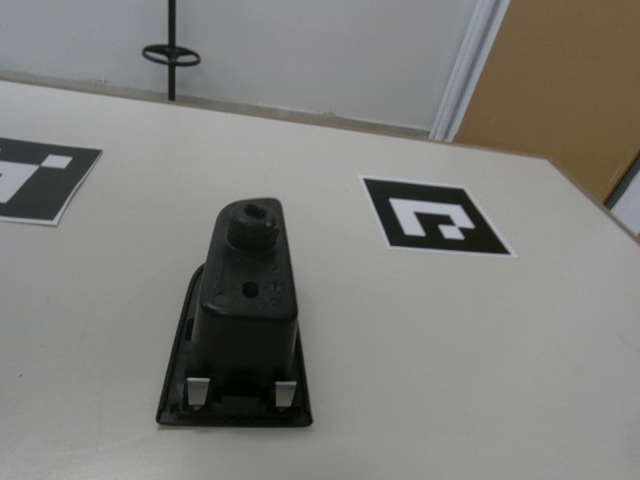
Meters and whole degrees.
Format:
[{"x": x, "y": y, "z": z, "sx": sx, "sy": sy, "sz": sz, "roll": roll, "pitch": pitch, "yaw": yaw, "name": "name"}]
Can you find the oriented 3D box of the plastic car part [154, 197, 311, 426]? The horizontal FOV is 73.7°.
[{"x": -0.036, "y": 0.020, "z": 0.209, "sx": 0.066, "sy": 0.071, "sz": 0.117, "roll": 6, "pitch": 40, "yaw": -12, "name": "plastic car part"}]
